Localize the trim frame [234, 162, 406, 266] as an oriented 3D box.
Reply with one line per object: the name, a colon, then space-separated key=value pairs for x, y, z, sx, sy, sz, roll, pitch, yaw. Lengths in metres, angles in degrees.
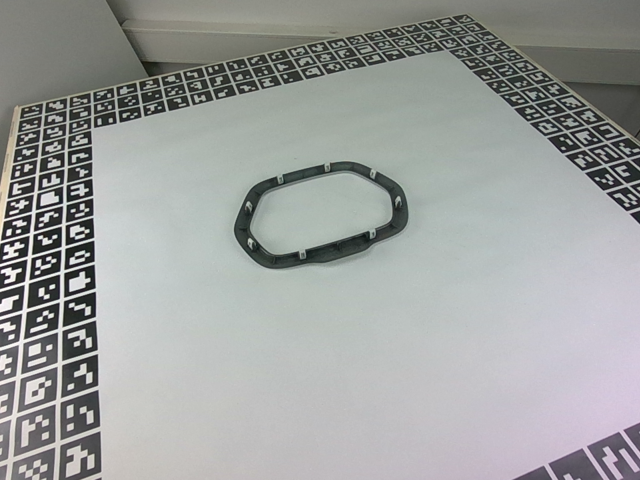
trim frame: x=0.001 y=-0.043 z=0.599 sx=0.248 sy=0.184 sz=0.027 roll=-14 pitch=-37 yaw=-12
